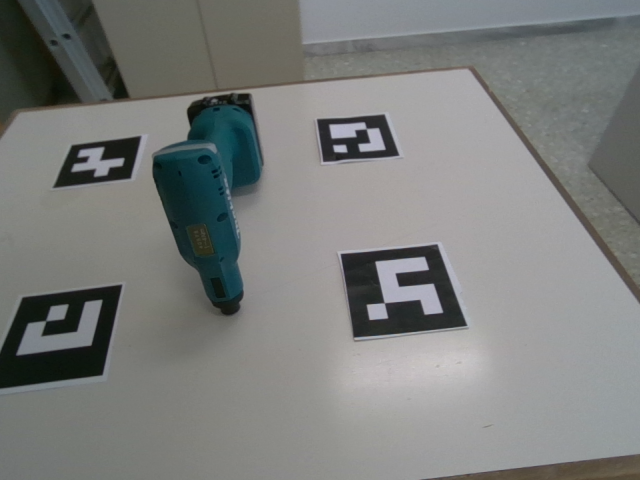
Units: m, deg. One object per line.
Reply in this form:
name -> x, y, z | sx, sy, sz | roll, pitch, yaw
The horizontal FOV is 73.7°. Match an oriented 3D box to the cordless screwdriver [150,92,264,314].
cordless screwdriver -> -0.100, -0.054, 0.443 | 0.074, 0.159, 0.249 | -9, 32, 1
